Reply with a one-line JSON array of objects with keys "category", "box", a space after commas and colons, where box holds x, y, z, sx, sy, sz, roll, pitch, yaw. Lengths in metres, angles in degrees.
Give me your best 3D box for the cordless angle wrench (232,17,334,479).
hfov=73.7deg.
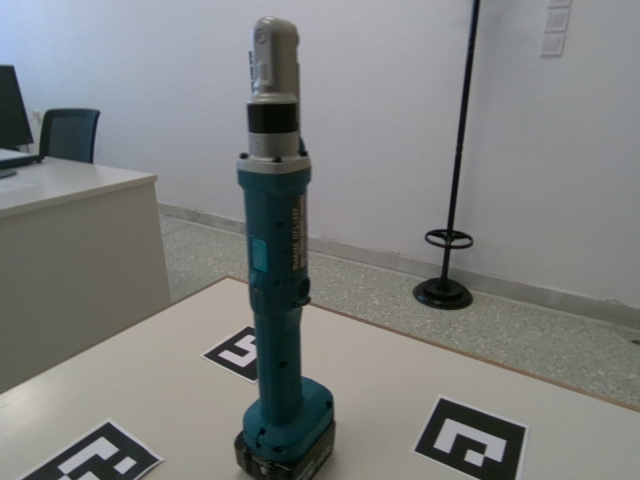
[{"category": "cordless angle wrench", "box": [-0.036, 0.037, 0.383, 0.075, 0.423, 0.097, 13, 24, 32]}]
